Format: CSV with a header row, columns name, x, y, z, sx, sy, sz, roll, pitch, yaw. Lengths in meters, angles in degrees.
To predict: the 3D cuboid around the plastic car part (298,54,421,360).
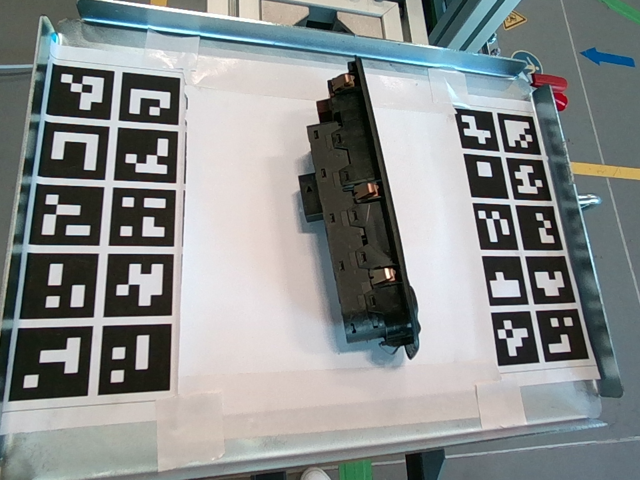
name,x,y,z,sx,sy,sz,roll,pitch,yaw
plastic car part,0.024,-0.018,0.289,0.067,0.203,0.066,-13,-14,-7
